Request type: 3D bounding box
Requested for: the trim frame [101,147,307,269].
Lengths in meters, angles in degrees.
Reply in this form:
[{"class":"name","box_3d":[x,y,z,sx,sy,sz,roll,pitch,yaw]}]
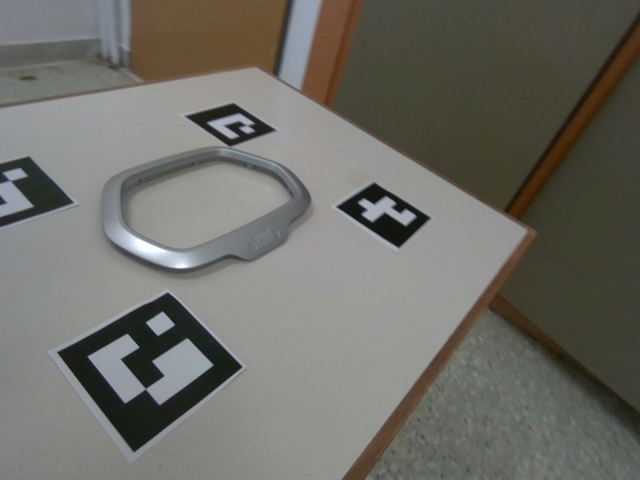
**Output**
[{"class":"trim frame","box_3d":[-0.125,-0.047,0.493,0.185,0.027,0.246,34,41,21]}]
